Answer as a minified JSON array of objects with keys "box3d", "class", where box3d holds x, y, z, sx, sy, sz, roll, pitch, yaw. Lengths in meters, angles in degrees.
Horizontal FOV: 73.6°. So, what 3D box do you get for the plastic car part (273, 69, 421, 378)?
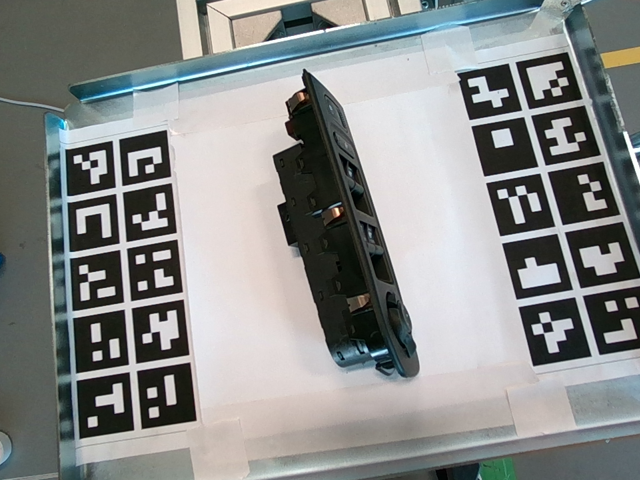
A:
[{"box3d":[0.011,-0.005,0.280,0.067,0.203,0.066,-23,-16,12],"class":"plastic car part"}]
